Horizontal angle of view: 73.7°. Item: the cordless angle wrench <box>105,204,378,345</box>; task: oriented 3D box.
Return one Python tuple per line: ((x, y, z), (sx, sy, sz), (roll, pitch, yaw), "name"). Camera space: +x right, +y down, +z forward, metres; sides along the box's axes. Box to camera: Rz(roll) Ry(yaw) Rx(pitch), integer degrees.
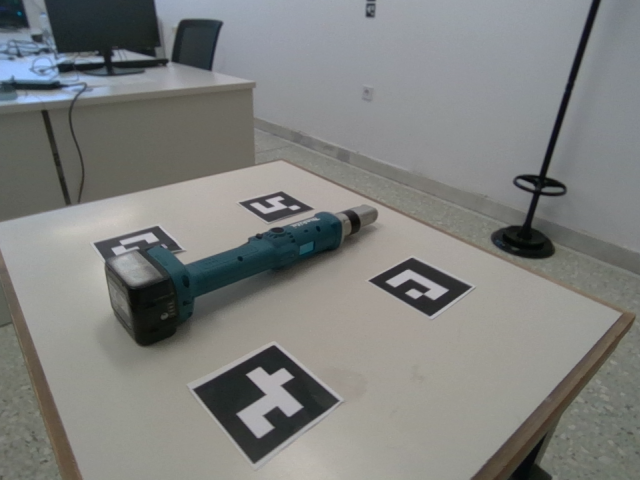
((-0.063, 0.011, 0.591), (0.418, 0.074, 0.099), (-21, 34, -38), "cordless angle wrench")
